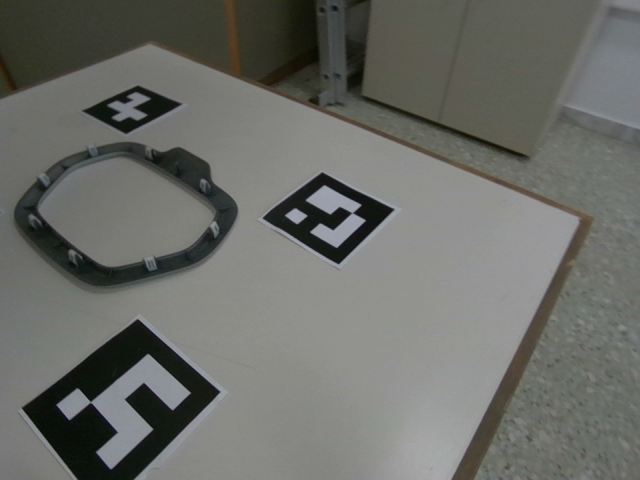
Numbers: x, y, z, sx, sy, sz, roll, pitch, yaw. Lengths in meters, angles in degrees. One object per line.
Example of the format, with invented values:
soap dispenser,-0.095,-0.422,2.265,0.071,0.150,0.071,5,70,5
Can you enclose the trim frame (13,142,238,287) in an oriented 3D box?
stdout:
trim frame,-0.202,-0.042,0.446,0.250,0.027,0.183,29,51,28
